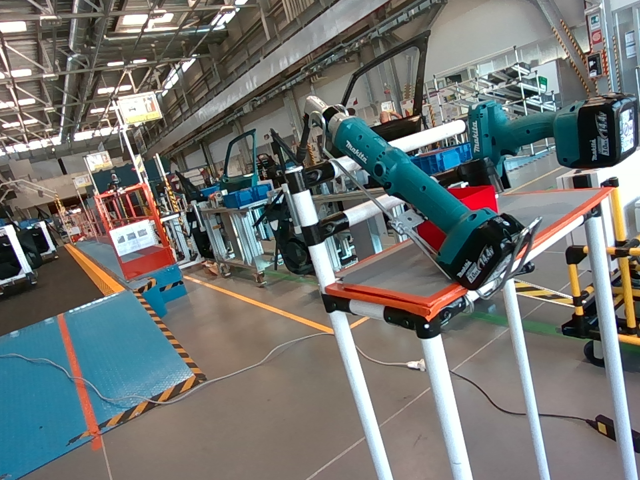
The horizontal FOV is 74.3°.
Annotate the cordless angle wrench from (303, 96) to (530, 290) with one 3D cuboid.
[{"bbox_3d":[0.106,-0.105,0.635,0.074,0.098,0.422,-20,55,-36],"label":"cordless angle wrench"}]

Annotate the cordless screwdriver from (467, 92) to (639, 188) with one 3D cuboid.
[{"bbox_3d":[0.352,-0.148,0.677,0.074,0.159,0.249,-25,24,-29],"label":"cordless screwdriver"}]
